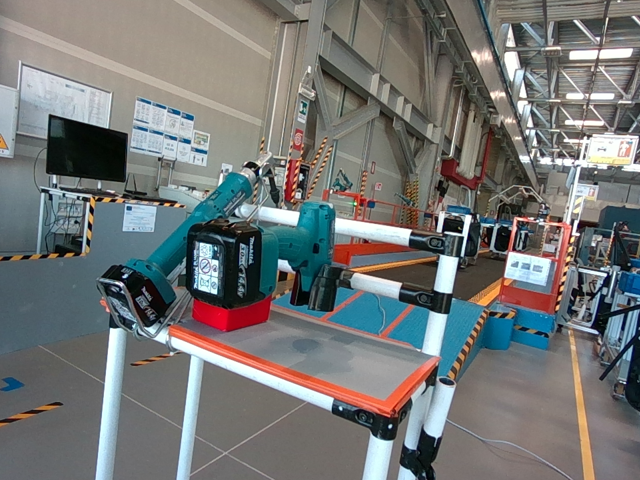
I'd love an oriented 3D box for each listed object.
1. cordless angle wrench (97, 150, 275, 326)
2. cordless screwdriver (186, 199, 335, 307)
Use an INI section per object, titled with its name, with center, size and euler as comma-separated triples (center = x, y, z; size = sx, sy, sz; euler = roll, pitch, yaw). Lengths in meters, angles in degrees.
[cordless angle wrench]
center = -0.202, -0.039, 0.763
size = 0.074, 0.098, 0.421
euler = 15, 50, 26
[cordless screwdriver]
center = -0.058, 0.034, 0.568
size = 0.074, 0.159, 0.248
euler = 8, 14, 32
